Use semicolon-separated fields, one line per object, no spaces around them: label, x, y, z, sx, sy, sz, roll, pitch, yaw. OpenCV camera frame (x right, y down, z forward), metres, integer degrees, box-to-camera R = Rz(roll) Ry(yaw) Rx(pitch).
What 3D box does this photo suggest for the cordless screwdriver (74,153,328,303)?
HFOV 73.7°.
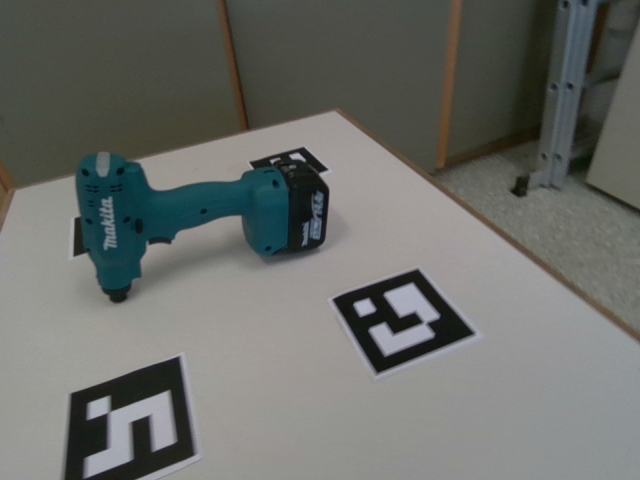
cordless screwdriver;-0.120;-0.012;0.466;0.247;0.159;0.075;-4;30;-21
